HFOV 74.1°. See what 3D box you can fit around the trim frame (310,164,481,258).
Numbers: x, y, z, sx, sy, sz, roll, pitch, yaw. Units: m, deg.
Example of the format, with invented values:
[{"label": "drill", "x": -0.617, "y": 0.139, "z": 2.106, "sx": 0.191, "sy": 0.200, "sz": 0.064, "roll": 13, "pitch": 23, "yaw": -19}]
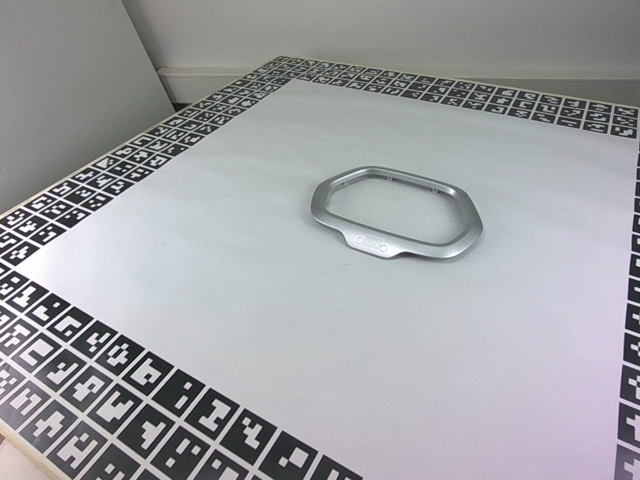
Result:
[{"label": "trim frame", "x": 0.104, "y": -0.047, "z": 0.614, "sx": 0.249, "sy": 0.027, "sz": 0.183, "roll": 20, "pitch": 48, "yaw": 20}]
